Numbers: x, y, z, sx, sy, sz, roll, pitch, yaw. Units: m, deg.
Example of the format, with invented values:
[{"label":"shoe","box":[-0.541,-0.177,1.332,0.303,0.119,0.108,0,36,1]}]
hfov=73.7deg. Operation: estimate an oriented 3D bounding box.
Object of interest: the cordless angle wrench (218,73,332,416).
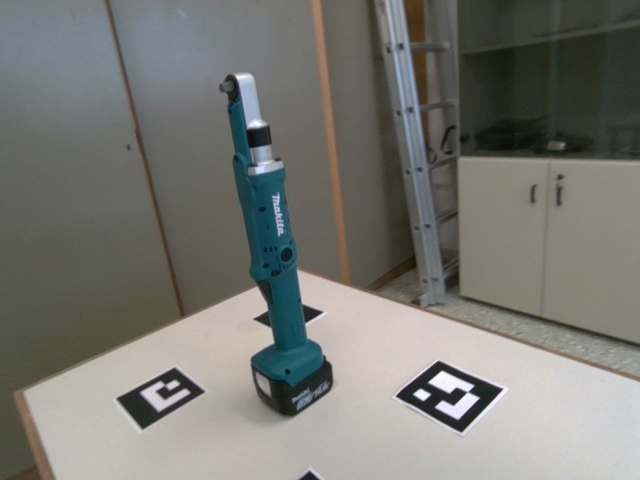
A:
[{"label":"cordless angle wrench","box":[-0.062,0.016,0.534,0.097,0.422,0.075,-22,23,-37]}]
